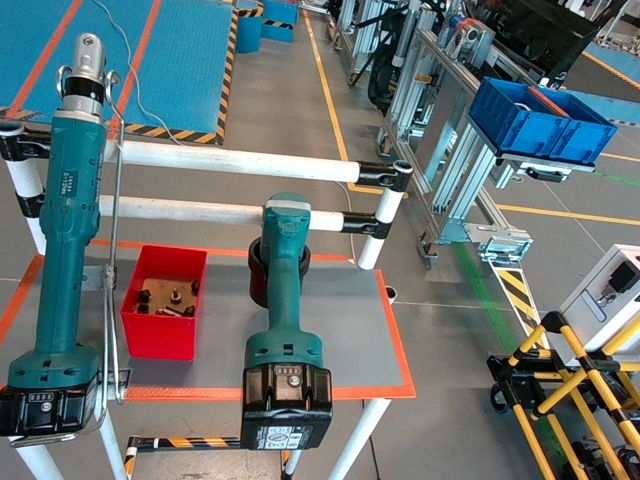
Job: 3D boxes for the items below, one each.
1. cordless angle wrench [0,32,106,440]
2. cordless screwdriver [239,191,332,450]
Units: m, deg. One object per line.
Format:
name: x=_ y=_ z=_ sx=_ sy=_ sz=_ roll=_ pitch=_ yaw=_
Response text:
cordless angle wrench: x=-0.267 y=-0.021 z=0.451 sx=0.074 sy=0.422 sz=0.098 roll=5 pitch=-7 yaw=-22
cordless screwdriver: x=-0.042 y=0.087 z=0.451 sx=0.074 sy=0.248 sz=0.160 roll=4 pitch=-39 yaw=-9
